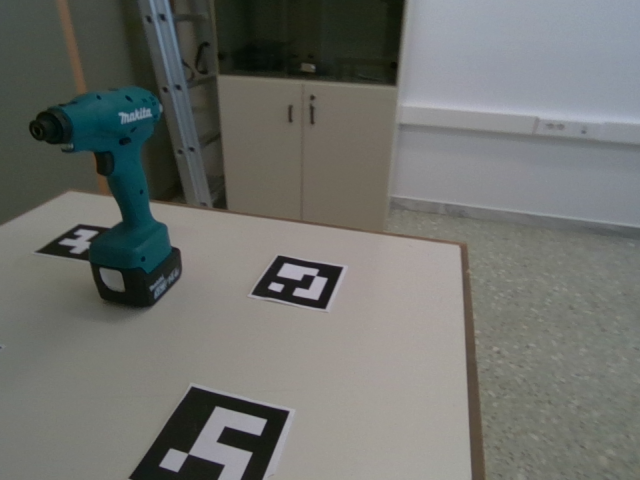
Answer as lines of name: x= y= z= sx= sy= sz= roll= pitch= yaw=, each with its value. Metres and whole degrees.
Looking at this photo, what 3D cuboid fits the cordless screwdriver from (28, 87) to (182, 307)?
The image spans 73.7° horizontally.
cordless screwdriver: x=-0.233 y=-0.038 z=0.484 sx=0.075 sy=0.249 sz=0.158 roll=8 pitch=26 yaw=12
